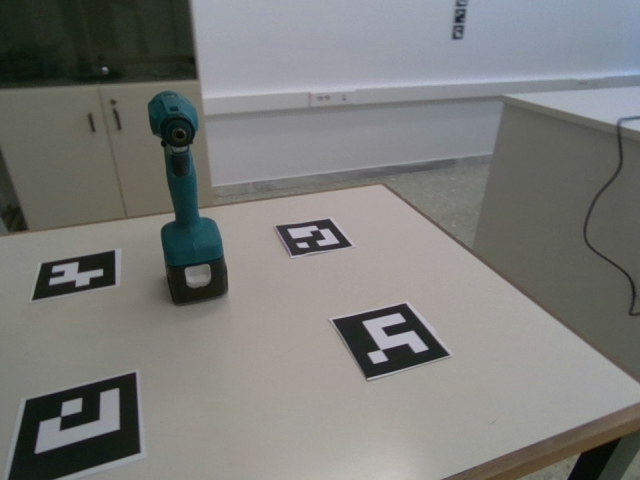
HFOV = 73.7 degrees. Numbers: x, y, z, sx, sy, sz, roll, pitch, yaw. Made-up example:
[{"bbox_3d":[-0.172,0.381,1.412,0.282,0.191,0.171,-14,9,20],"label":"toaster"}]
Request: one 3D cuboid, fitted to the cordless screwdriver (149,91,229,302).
[{"bbox_3d":[-0.157,-0.040,0.505,0.074,0.248,0.160,-9,27,-18],"label":"cordless screwdriver"}]
